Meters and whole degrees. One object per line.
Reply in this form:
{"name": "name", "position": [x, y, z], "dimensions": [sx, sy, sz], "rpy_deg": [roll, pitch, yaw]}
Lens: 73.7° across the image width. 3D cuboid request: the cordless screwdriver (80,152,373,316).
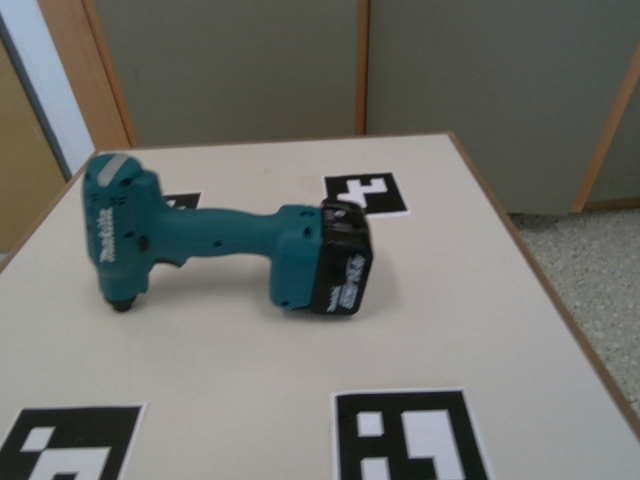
{"name": "cordless screwdriver", "position": [-0.085, 0.020, 0.393], "dimensions": [0.248, 0.159, 0.074], "rpy_deg": [10, 34, -7]}
